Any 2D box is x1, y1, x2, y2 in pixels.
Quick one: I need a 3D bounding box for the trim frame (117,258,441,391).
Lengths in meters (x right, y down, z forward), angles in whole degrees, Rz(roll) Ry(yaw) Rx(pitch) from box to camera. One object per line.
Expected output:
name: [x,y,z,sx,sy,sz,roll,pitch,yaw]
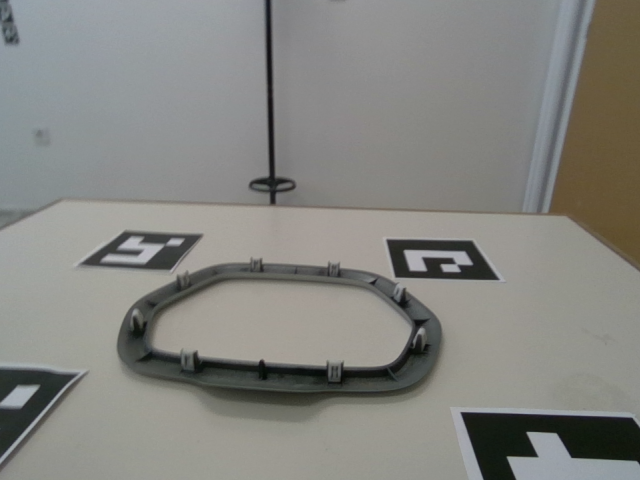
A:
trim frame: [-0.032,0.058,0.339,0.249,0.027,0.184,4,24,6]
